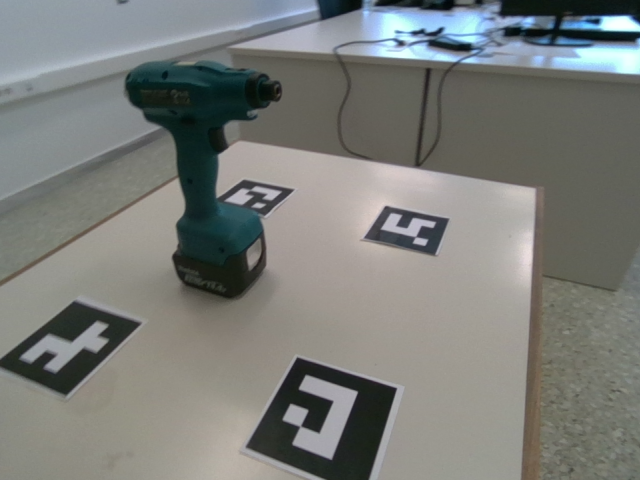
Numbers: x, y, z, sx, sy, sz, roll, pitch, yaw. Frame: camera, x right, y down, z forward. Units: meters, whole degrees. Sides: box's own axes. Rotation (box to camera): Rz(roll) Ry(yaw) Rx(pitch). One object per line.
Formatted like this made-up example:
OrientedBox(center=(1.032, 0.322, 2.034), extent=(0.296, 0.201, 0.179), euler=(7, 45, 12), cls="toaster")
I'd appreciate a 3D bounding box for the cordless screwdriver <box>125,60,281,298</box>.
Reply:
OrientedBox(center=(-0.102, -0.057, 0.452), extent=(0.160, 0.248, 0.074), euler=(10, 34, 24), cls="cordless screwdriver")
